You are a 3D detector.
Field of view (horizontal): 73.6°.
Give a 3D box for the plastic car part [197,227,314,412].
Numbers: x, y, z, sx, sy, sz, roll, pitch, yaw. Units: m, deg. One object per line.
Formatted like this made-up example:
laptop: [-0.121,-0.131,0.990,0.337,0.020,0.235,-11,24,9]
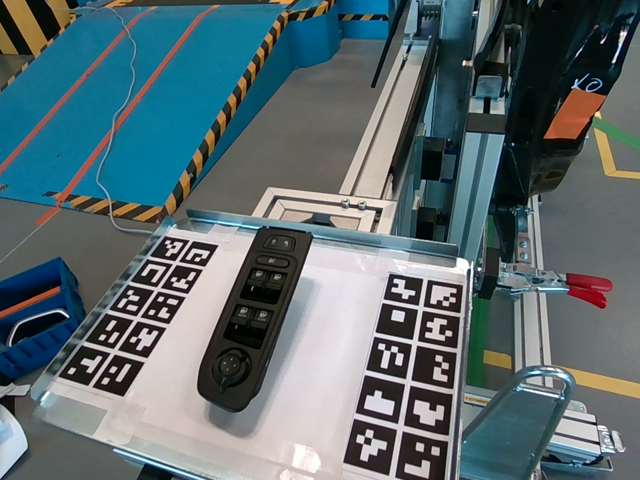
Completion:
plastic car part: [-0.065,0.079,0.447,0.066,0.202,0.067,13,-38,9]
